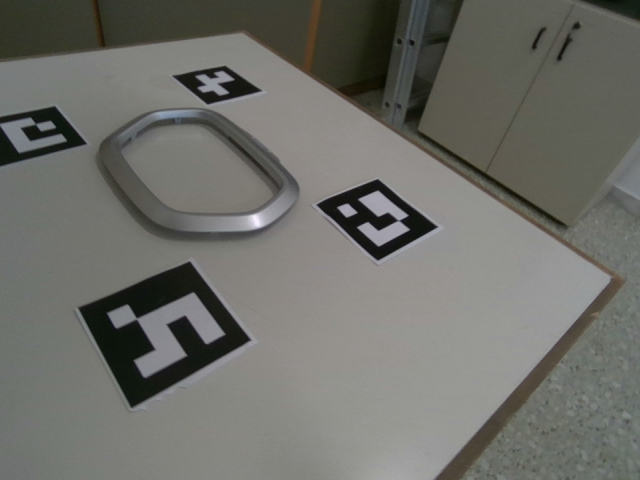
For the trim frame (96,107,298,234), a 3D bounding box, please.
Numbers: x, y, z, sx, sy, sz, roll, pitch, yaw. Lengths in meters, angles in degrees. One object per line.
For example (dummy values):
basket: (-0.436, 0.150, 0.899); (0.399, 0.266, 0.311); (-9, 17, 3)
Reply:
trim frame: (-0.137, -0.087, 0.481); (0.182, 0.027, 0.250); (-28, 54, -31)
